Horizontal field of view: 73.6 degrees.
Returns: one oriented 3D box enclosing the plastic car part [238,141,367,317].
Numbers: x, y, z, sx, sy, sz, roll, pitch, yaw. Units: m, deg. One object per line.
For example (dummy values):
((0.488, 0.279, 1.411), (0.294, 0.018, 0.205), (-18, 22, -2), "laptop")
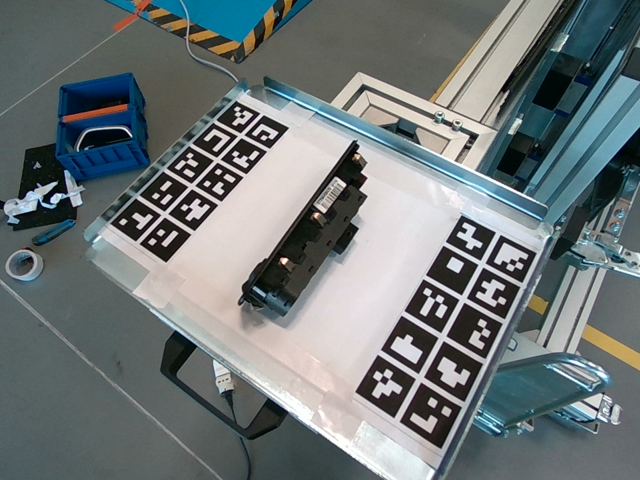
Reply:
((-0.008, -0.003, 0.426), (0.067, 0.202, 0.067), (43, -23, -8), "plastic car part")
